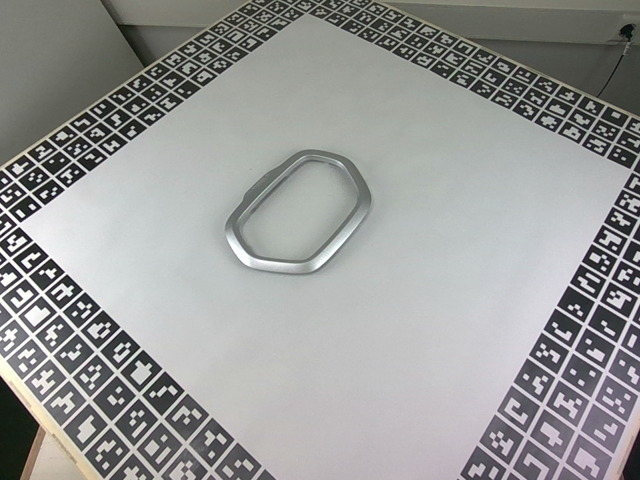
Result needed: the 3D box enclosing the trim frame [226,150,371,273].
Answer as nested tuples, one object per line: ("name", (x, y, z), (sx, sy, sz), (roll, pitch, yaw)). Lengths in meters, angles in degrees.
("trim frame", (-0.032, -0.051, 0.665), (0.184, 0.247, 0.027), (32, -23, 17))
